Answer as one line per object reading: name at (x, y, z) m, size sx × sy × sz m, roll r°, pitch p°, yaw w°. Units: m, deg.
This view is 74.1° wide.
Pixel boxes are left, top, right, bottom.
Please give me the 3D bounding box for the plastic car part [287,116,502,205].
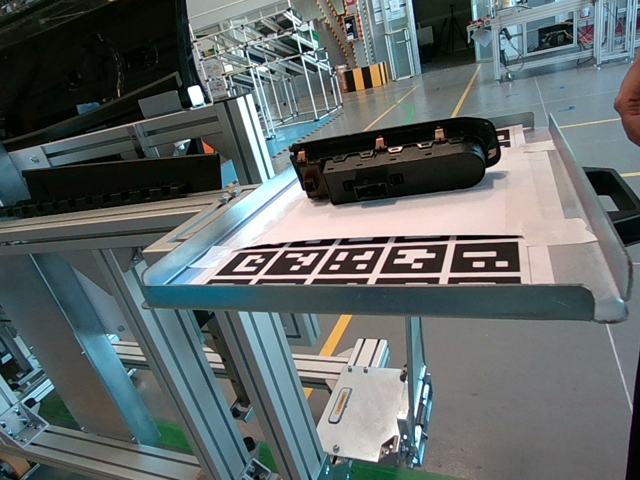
plastic car part at (0.069, -0.071, 0.405) m, size 0.204 × 0.066 × 0.067 m, roll -8°, pitch 38°, yaw 14°
